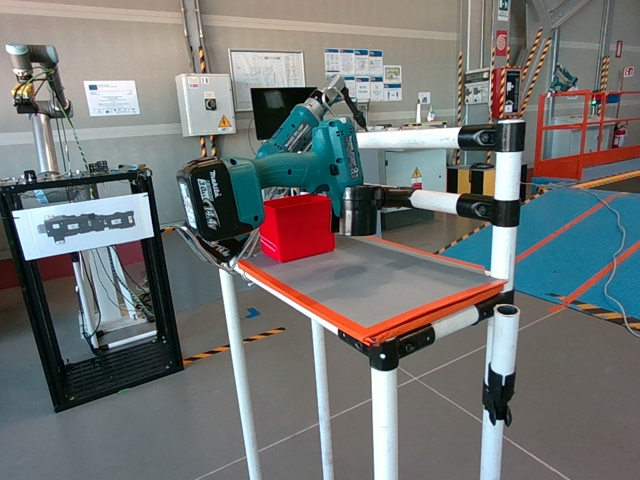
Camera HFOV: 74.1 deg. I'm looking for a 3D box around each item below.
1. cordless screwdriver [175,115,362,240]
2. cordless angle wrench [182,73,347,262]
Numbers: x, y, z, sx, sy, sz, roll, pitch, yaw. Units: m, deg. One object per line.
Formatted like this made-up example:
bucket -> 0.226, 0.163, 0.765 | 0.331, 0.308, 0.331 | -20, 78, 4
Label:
cordless screwdriver -> -0.049, -0.061, 0.558 | 0.248, 0.159, 0.074 | -22, 21, -26
cordless angle wrench -> -0.083, -0.153, 0.785 | 0.098, 0.422, 0.074 | 44, -13, -35
